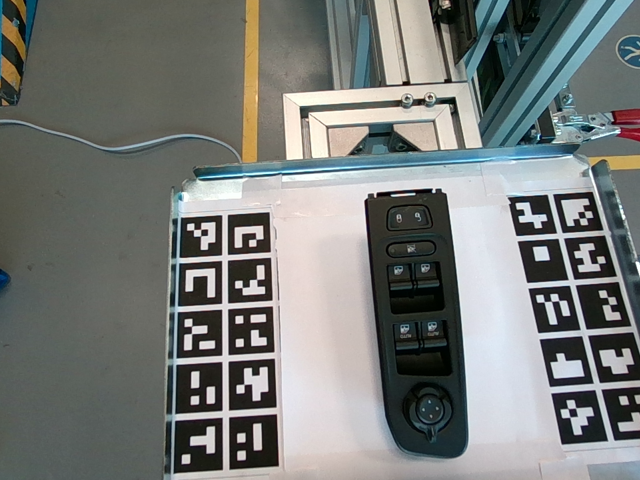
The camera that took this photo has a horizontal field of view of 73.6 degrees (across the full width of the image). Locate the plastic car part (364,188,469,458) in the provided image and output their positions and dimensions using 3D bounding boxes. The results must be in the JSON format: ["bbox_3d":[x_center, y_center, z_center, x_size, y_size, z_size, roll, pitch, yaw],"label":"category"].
[{"bbox_3d":[0.072,0.064,0.344,0.066,0.202,0.067,-3,-14,-9],"label":"plastic car part"}]
